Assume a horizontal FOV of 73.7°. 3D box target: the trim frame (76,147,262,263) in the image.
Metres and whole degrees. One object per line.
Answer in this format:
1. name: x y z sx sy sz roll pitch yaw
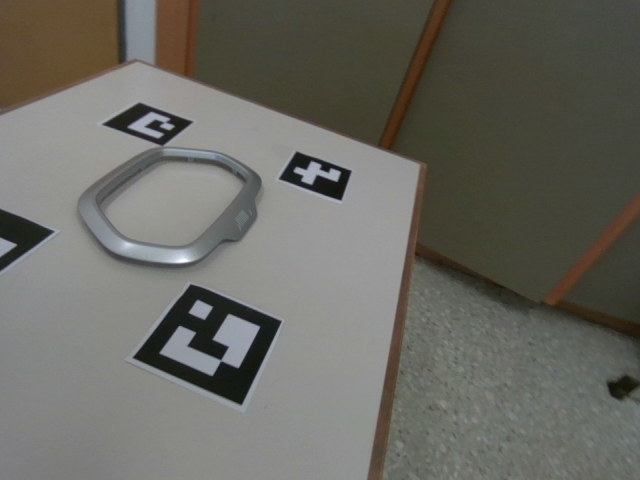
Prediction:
1. trim frame: -0.169 -0.053 0.520 0.184 0.027 0.247 18 36 4
